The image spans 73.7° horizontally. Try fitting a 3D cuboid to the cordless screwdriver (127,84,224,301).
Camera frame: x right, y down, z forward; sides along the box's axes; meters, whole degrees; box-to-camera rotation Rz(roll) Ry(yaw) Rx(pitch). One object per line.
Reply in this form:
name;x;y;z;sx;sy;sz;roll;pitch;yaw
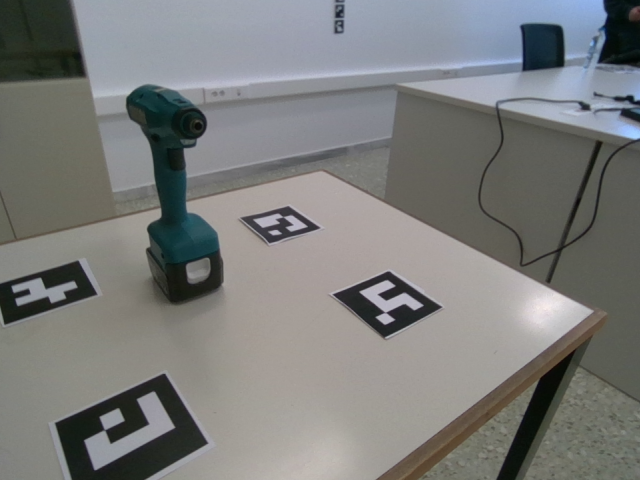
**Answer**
cordless screwdriver;-0.161;-0.045;0.497;0.073;0.248;0.161;-18;31;-32
